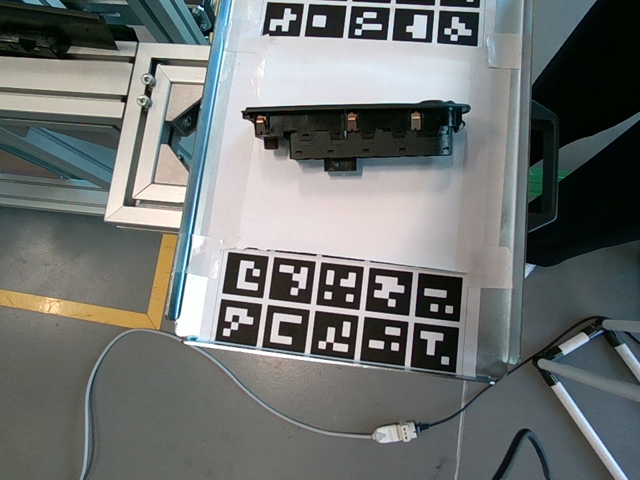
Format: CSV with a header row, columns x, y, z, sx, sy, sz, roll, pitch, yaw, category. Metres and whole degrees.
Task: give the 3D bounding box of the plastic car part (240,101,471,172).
x,y,z,sx,sy,sz,roll,pitch,yaw,category
0.035,-0.096,0.387,0.203,0.067,0.066,-5,0,3,plastic car part
